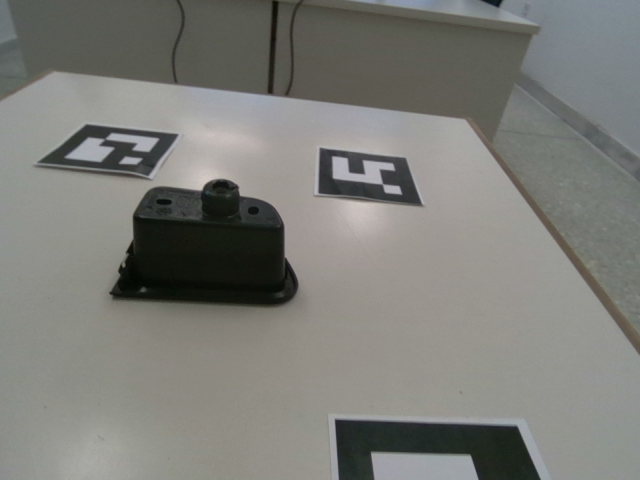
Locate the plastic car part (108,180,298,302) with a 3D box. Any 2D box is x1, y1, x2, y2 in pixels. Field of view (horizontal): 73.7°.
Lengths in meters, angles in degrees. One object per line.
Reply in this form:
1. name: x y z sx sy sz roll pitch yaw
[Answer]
1. plastic car part: -0.071 -0.004 0.275 0.116 0.071 0.066 2 37 -2
